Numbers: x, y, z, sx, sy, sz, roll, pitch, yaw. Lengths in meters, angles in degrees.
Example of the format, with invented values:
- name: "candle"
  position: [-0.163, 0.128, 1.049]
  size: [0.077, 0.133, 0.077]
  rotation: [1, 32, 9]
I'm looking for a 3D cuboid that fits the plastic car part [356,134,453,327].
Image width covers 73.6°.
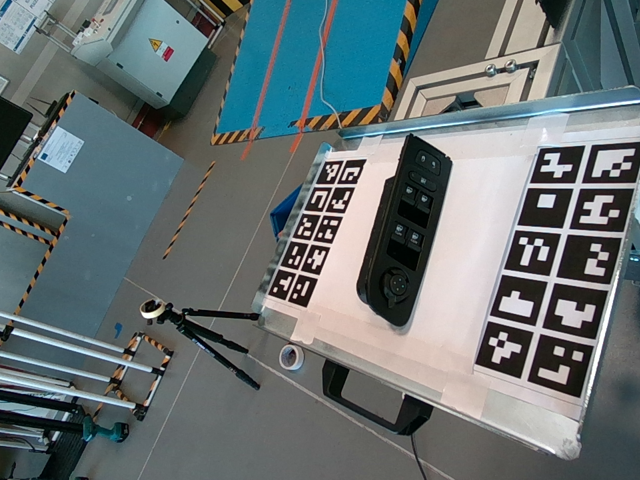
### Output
- name: "plastic car part"
  position: [0.082, -0.010, 0.462]
  size: [0.066, 0.202, 0.067]
  rotation: [27, -23, -28]
